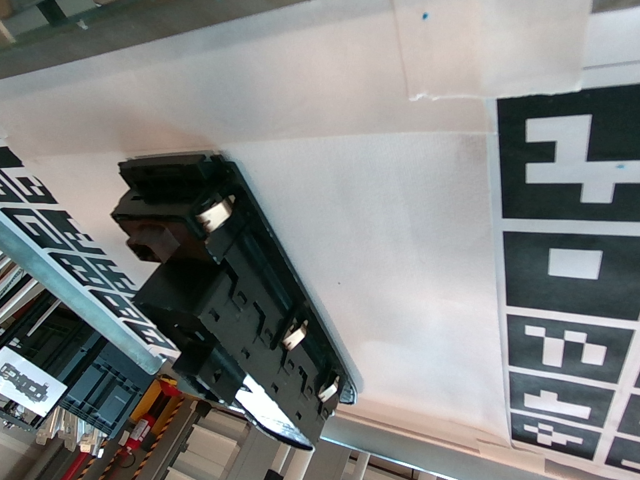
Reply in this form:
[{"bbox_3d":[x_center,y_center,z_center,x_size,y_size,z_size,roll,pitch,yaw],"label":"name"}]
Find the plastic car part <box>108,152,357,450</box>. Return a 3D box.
[{"bbox_3d":[-0.032,0.053,0.218,0.067,0.067,0.202,-3,-42,25],"label":"plastic car part"}]
